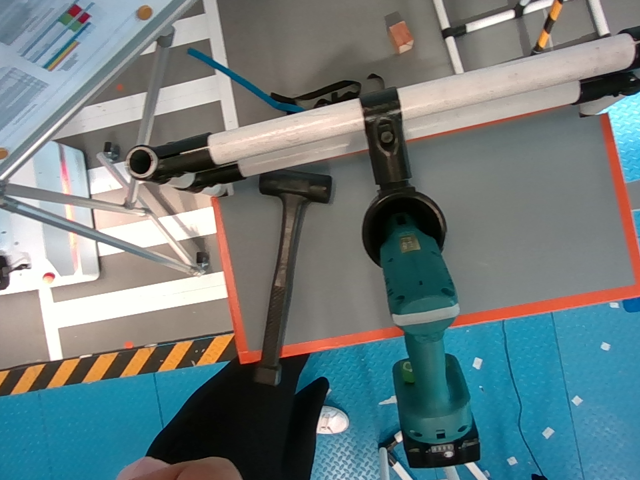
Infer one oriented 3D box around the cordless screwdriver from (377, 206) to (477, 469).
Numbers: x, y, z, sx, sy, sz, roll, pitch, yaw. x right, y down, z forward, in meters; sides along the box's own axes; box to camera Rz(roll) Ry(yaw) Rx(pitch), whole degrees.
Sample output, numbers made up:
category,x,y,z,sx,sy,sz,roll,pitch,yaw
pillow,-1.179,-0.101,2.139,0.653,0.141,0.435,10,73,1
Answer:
category,x,y,z,sx,sy,sz,roll,pitch,yaw
cordless screwdriver,0.097,0.096,0.420,0.074,0.249,0.159,-10,30,7
